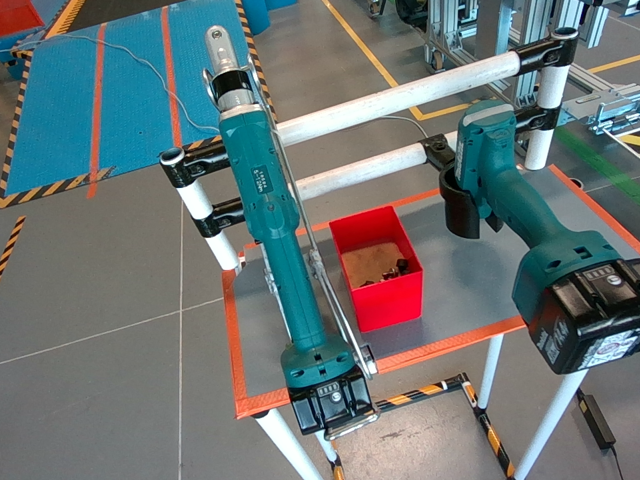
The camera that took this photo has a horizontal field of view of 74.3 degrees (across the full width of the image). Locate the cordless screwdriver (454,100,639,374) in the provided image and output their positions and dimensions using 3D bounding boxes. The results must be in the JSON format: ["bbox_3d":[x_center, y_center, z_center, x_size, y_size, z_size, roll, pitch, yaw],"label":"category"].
[{"bbox_3d":[0.197,0.000,0.406,0.074,0.248,0.159,-17,-36,2],"label":"cordless screwdriver"}]

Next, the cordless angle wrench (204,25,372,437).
[{"bbox_3d":[-0.050,-0.023,0.440,0.074,0.422,0.098,-17,-3,-10],"label":"cordless angle wrench"}]
